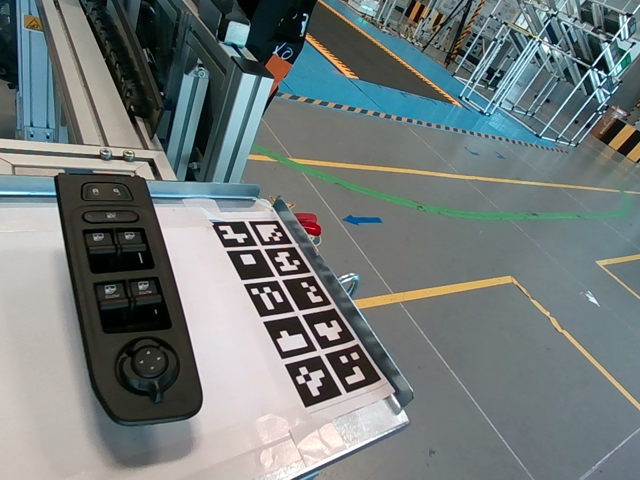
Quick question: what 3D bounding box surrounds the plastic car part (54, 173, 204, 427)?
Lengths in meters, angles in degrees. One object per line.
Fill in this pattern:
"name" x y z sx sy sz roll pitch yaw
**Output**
"plastic car part" -0.141 0.040 0.299 0.066 0.203 0.067 3 -45 -44
